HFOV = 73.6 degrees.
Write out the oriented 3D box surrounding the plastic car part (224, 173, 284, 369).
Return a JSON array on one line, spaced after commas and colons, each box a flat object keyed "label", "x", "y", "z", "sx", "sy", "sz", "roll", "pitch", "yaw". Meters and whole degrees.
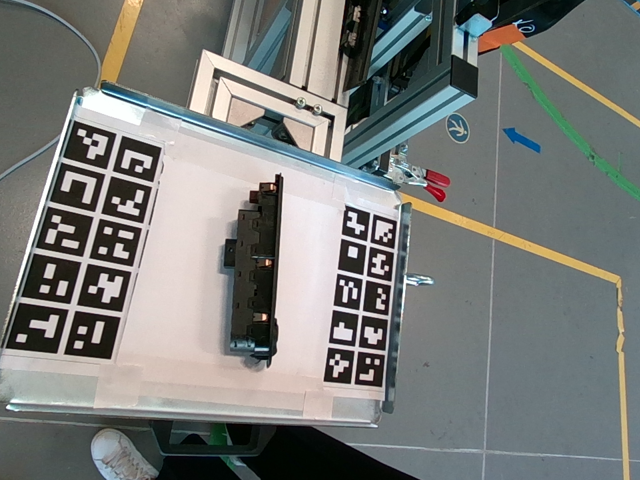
[{"label": "plastic car part", "x": -0.067, "y": 0.034, "z": 0.448, "sx": 0.067, "sy": 0.202, "sz": 0.066, "roll": 1, "pitch": -12, "yaw": -17}]
